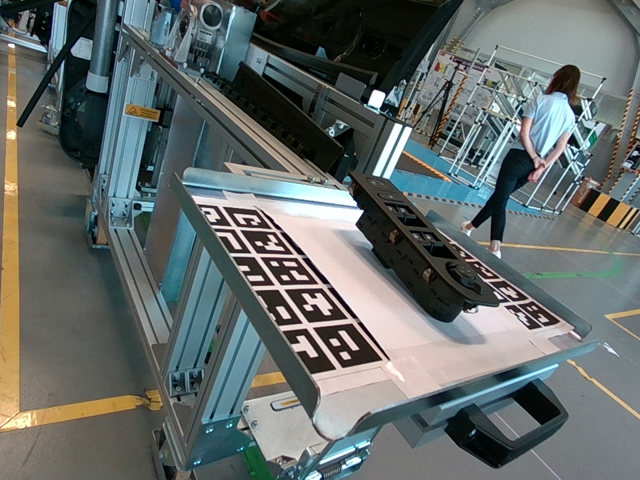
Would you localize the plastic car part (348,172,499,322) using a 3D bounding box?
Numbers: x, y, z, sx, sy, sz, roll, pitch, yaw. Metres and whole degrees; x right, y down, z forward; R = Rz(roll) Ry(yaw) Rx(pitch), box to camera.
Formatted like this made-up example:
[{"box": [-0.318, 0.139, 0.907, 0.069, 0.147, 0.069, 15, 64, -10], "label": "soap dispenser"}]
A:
[{"box": [0.091, 0.007, 0.442, 0.066, 0.067, 0.203, 12, 29, -44], "label": "plastic car part"}]
